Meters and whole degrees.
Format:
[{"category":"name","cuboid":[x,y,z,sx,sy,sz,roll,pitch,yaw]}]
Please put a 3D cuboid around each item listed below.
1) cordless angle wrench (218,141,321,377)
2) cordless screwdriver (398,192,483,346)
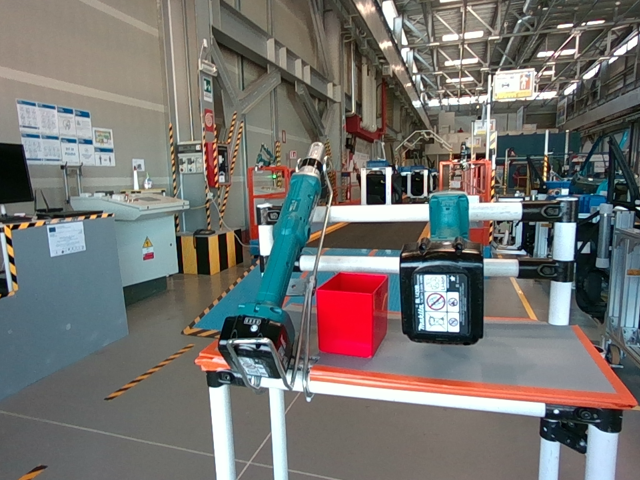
[{"category":"cordless angle wrench","cuboid":[-0.046,-0.010,0.653,0.074,0.421,0.098,6,-36,11]},{"category":"cordless screwdriver","cuboid":[0.147,0.043,0.491,0.074,0.159,0.248,0,18,19]}]
